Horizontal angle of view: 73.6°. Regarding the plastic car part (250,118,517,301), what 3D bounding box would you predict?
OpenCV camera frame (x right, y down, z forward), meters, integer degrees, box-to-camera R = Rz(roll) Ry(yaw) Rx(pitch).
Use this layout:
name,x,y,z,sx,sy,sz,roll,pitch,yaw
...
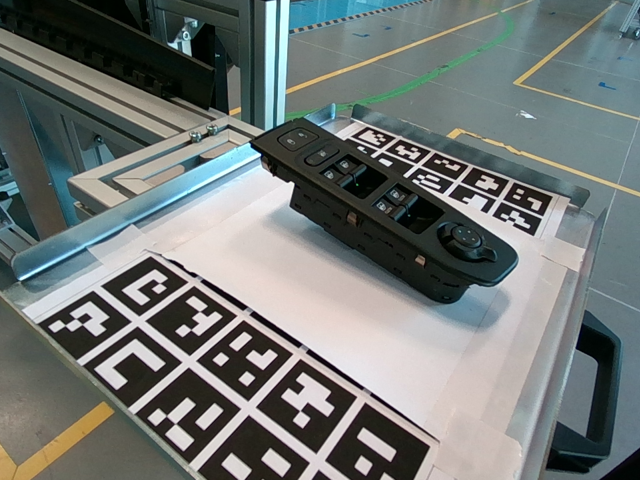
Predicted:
name,x,y,z,sx,sy,sz,roll,pitch,yaw
plastic car part,0.039,-0.018,0.320,0.203,0.067,0.066,31,36,19
